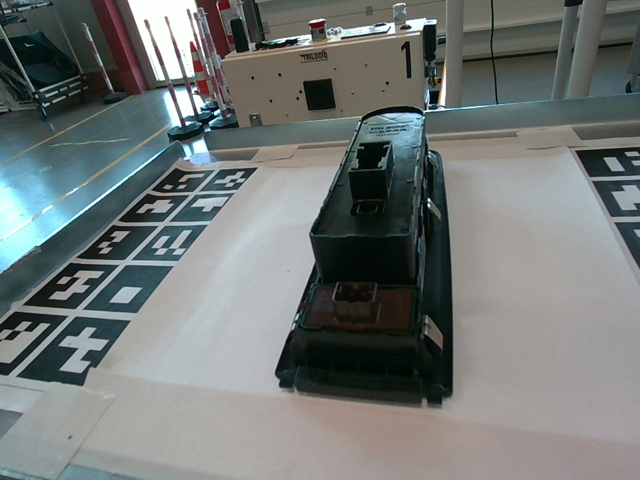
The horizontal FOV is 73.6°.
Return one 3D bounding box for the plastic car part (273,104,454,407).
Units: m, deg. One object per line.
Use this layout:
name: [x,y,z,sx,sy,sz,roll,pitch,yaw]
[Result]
plastic car part: [0.030,-0.020,0.219,0.067,0.067,0.202,-6,30,20]
